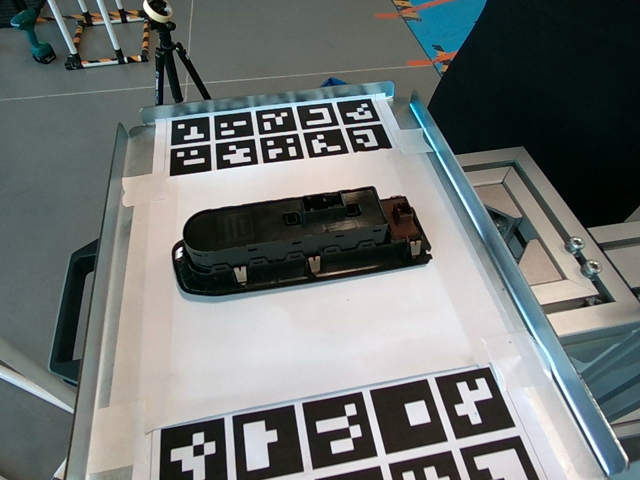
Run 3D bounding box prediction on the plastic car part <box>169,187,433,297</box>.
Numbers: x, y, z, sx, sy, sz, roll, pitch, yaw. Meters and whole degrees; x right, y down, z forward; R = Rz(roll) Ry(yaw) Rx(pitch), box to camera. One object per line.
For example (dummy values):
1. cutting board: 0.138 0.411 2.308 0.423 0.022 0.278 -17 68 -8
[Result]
1. plastic car part: -0.016 -0.002 0.324 0.203 0.066 0.067 -11 -31 -5
